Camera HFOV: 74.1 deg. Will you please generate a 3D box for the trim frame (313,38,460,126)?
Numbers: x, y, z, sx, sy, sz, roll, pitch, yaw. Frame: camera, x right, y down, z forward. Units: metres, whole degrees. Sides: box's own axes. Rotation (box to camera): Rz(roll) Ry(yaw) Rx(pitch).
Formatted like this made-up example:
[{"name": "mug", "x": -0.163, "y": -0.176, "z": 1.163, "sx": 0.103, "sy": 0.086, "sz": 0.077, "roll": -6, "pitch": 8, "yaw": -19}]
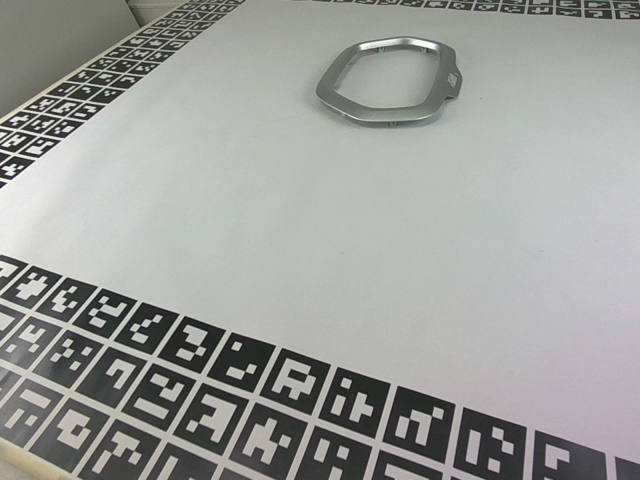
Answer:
[{"name": "trim frame", "x": 0.095, "y": -0.223, "z": 0.577, "sx": 0.185, "sy": 0.027, "sz": 0.247, "roll": 11, "pitch": 46, "yaw": 16}]
